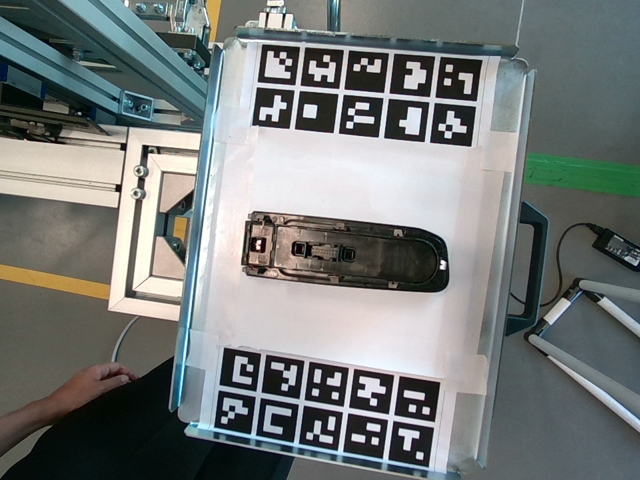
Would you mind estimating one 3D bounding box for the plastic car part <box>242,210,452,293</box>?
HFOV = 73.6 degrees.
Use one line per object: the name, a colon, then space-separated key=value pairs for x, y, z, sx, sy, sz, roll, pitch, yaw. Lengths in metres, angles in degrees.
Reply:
plastic car part: x=0.024 y=0.011 z=0.398 sx=0.203 sy=0.066 sz=0.067 roll=6 pitch=-6 yaw=4
